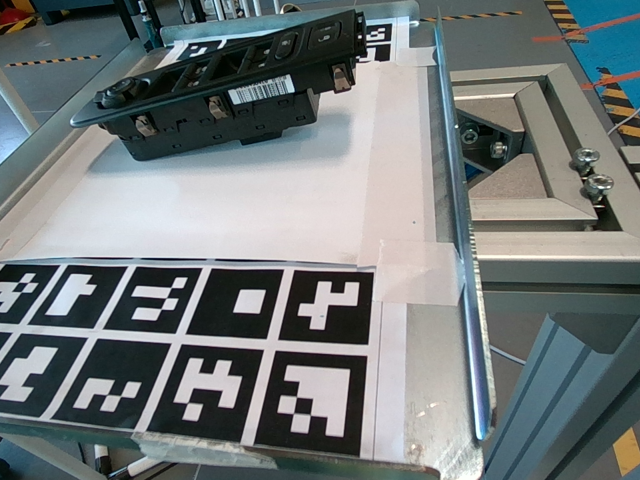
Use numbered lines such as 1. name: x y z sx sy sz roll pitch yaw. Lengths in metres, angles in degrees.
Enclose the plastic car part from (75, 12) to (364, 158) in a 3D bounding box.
1. plastic car part: -0.068 -0.098 0.293 0.204 0.066 0.067 -4 -34 14
